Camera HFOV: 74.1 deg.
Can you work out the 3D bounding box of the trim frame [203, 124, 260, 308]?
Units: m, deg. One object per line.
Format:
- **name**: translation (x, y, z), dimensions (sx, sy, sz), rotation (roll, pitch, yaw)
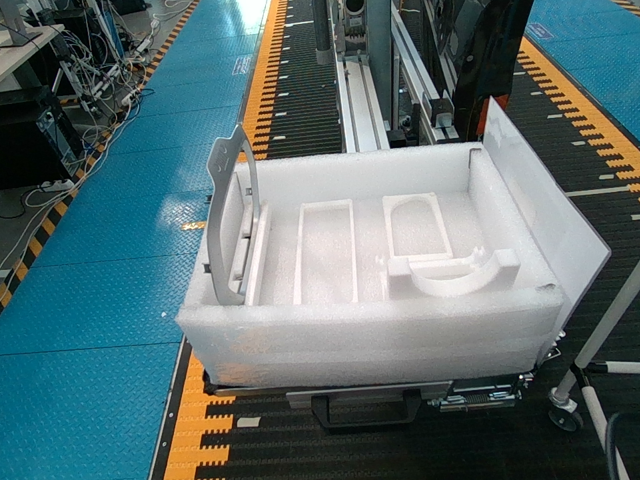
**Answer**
- **trim frame**: translation (-0.104, -0.032, 0.521), dimensions (0.027, 0.247, 0.184), rotation (1, -43, 4)
